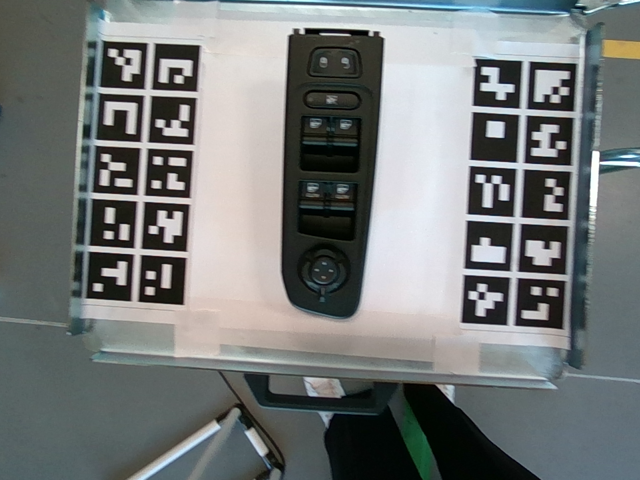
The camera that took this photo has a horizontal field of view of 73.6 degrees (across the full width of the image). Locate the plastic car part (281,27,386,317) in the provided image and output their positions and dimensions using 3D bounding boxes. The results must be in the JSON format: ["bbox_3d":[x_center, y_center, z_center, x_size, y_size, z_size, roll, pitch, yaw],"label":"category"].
[{"bbox_3d":[0.004,-0.044,0.324,0.066,0.203,0.067,2,6,-7],"label":"plastic car part"}]
